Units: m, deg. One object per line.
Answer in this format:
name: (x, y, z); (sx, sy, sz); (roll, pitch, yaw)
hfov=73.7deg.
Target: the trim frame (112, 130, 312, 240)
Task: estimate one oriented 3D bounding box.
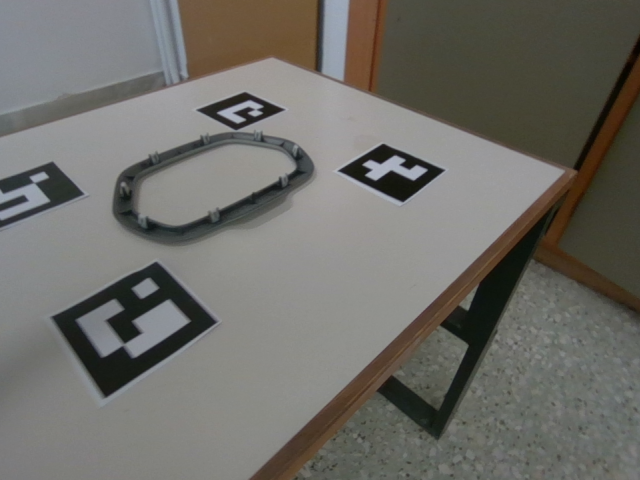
trim frame: (-0.125, -0.078, 0.511); (0.246, 0.027, 0.185); (-31, 51, -33)
